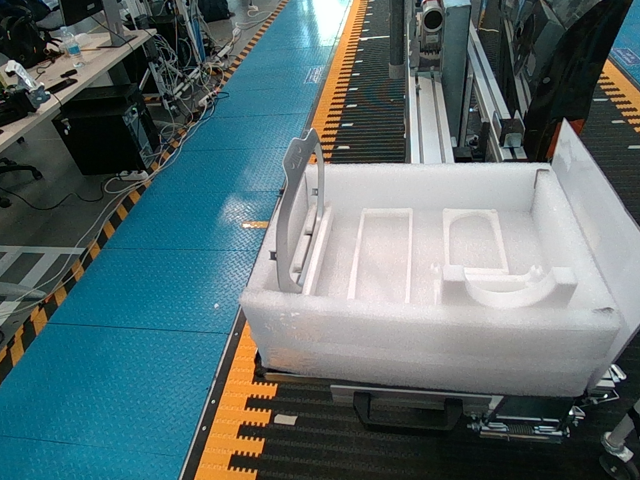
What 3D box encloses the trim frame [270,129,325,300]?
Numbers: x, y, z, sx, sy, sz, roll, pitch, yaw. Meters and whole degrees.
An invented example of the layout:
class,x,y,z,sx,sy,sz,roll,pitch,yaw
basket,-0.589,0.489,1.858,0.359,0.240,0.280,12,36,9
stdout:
class,x,y,z,sx,sy,sz,roll,pitch,yaw
trim frame,-0.023,-0.036,0.549,0.027,0.184,0.247,5,45,11
